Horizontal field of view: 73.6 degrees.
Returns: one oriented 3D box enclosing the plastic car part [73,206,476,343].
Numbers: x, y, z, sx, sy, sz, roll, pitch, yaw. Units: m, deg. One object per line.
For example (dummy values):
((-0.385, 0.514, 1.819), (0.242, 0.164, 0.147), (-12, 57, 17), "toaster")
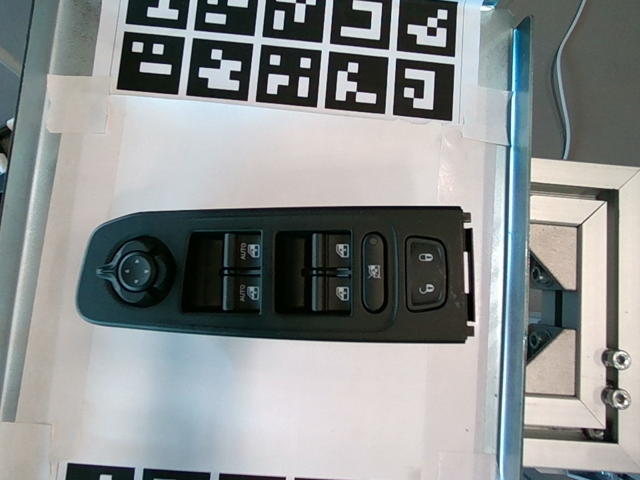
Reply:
((-0.027, 0.016, 0.234), (0.203, 0.066, 0.067), (0, 0, 1), "plastic car part")
